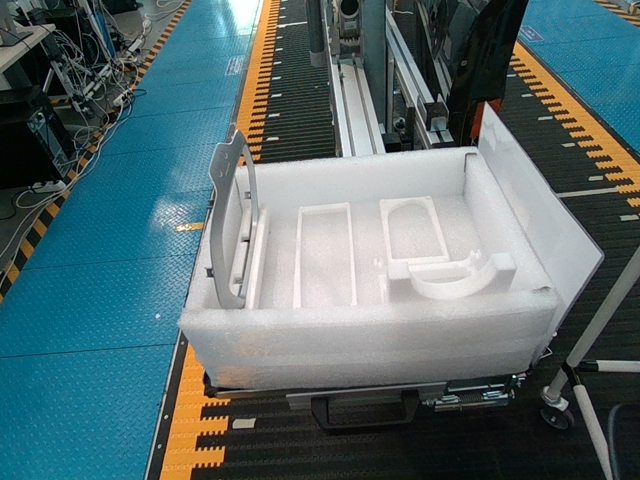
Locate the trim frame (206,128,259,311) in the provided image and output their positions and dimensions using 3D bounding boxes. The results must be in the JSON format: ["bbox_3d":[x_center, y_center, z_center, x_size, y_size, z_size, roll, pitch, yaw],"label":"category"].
[{"bbox_3d":[-0.104,-0.027,0.525,0.027,0.247,0.184,1,-42,3],"label":"trim frame"}]
